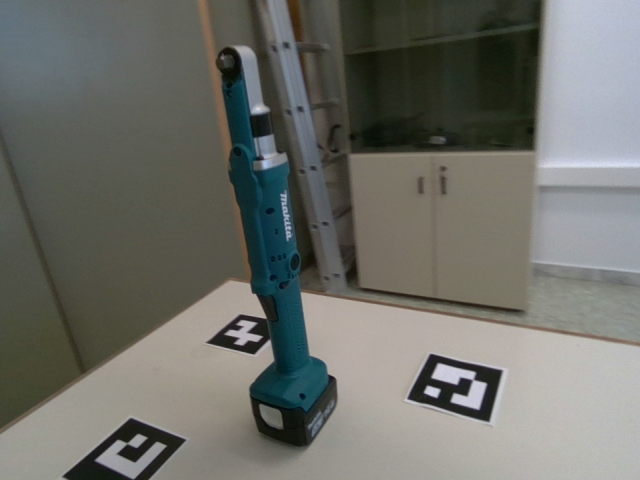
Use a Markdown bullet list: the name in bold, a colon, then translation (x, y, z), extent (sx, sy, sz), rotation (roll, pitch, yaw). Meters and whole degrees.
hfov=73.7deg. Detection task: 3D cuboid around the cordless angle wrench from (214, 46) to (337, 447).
- **cordless angle wrench**: translation (-0.051, 0.023, 0.455), extent (0.075, 0.422, 0.097), rotation (4, 23, 29)
